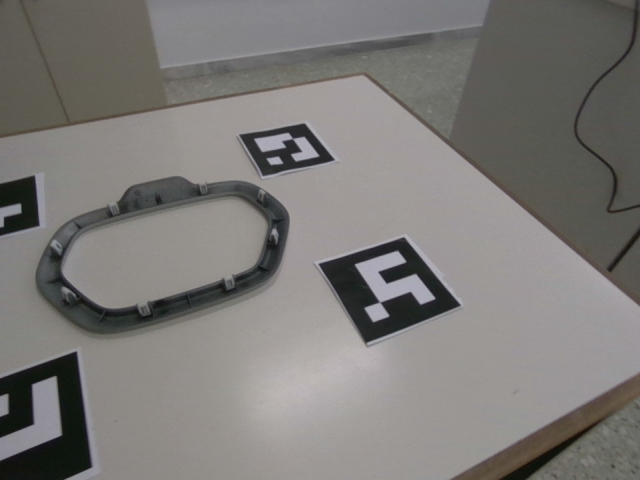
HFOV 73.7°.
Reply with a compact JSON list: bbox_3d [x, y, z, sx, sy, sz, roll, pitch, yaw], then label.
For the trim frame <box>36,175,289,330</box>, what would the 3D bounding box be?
[{"bbox_3d":[-0.150,-0.002,0.430,0.247,0.027,0.185,-17,48,-15],"label":"trim frame"}]
